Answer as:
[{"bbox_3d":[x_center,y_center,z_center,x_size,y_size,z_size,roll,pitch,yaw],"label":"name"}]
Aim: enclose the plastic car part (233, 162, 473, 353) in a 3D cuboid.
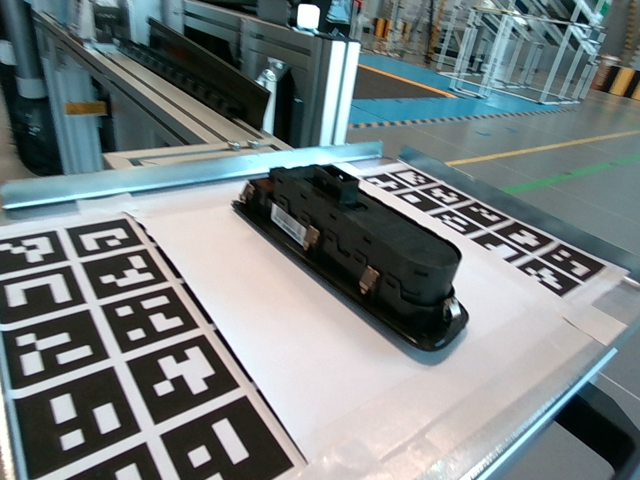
[{"bbox_3d":[0.020,-0.008,0.291,0.066,0.067,0.203,-11,39,-39],"label":"plastic car part"}]
